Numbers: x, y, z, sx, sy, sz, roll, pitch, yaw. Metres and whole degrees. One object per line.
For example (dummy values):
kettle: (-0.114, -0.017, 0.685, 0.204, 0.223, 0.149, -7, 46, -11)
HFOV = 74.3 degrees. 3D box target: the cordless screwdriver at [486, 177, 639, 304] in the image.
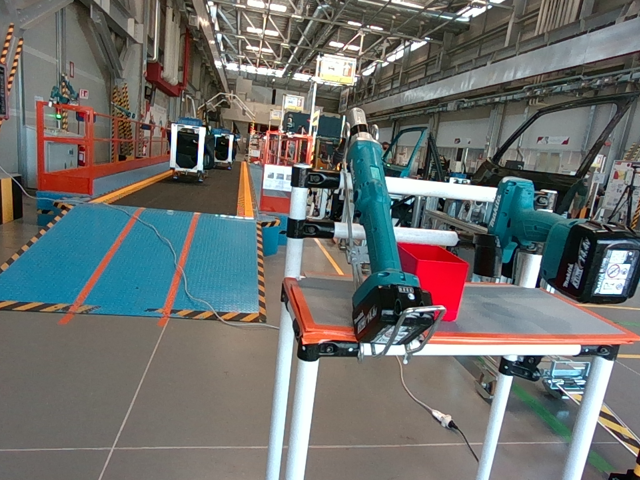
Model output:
cordless screwdriver: (0.321, 0.014, 0.607, 0.074, 0.159, 0.248, 2, 22, -11)

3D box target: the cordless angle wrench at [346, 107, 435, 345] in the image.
cordless angle wrench: (0.078, -0.058, 0.640, 0.074, 0.421, 0.098, 8, -36, -18)
